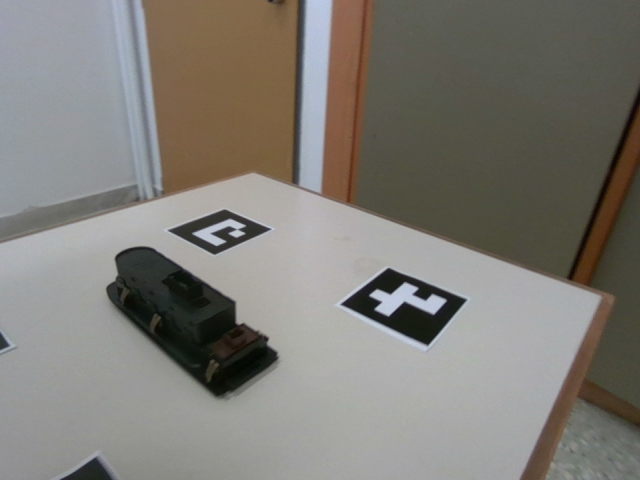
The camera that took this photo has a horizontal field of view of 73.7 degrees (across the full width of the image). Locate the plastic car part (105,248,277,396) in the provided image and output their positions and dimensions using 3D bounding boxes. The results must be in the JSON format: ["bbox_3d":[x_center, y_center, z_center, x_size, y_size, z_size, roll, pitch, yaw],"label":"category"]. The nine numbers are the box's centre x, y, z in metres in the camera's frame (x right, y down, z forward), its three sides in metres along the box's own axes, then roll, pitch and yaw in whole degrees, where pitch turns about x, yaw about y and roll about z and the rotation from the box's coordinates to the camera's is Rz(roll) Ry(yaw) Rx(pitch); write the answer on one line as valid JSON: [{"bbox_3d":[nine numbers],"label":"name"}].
[{"bbox_3d":[-0.133,0.058,0.390,0.205,0.067,0.066,20,37,36],"label":"plastic car part"}]
